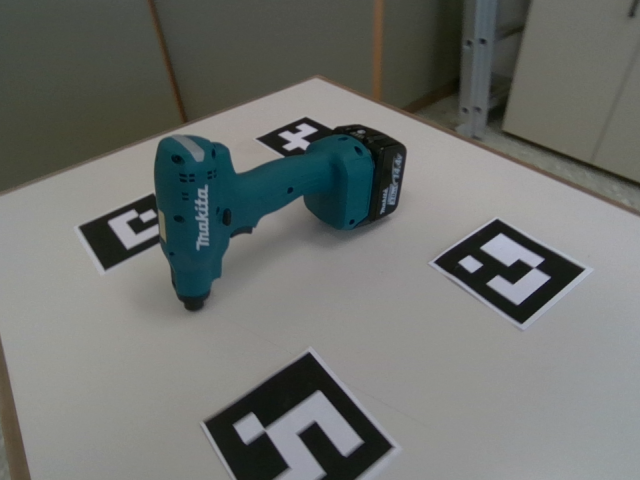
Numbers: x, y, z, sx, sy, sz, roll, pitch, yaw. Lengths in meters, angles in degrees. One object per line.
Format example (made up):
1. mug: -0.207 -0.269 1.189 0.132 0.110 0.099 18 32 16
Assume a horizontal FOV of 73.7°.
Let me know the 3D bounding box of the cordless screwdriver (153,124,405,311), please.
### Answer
1. cordless screwdriver: -0.033 -0.029 0.419 0.246 0.159 0.075 -16 36 -34
